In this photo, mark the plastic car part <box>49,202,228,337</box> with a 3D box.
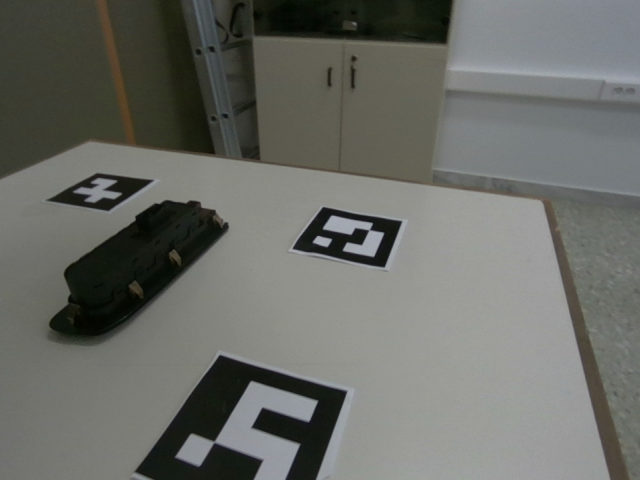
[{"bbox_3d":[-0.162,0.011,0.403,0.066,0.067,0.202,15,37,11],"label":"plastic car part"}]
